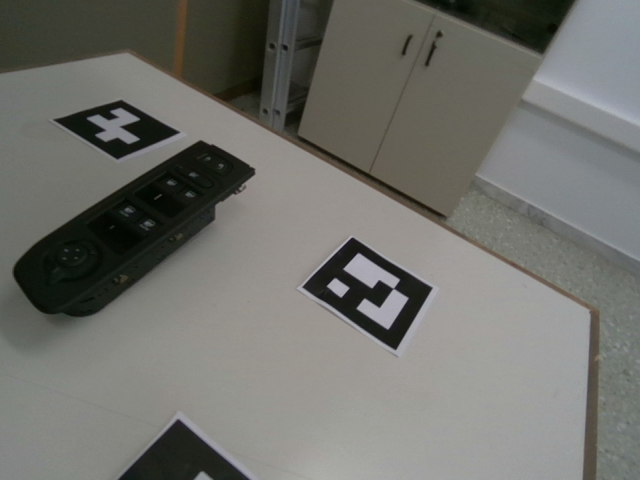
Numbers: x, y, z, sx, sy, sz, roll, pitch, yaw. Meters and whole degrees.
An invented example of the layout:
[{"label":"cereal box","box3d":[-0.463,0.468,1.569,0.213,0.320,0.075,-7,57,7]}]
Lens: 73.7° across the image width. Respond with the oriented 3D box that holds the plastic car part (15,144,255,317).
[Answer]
[{"label":"plastic car part","box3d":[-0.143,-0.009,0.351,0.066,0.067,0.201,36,45,9]}]
